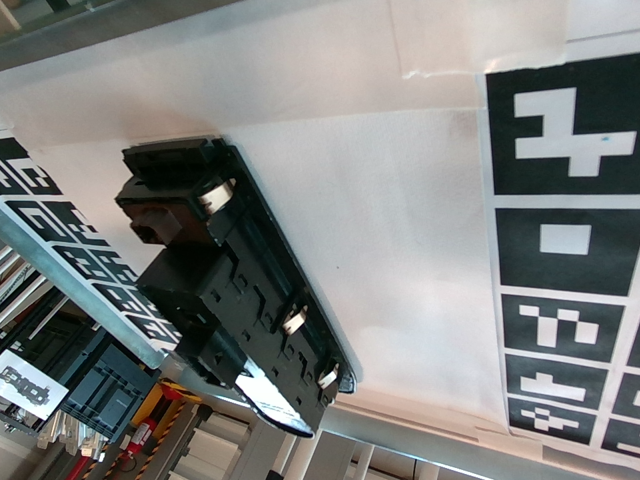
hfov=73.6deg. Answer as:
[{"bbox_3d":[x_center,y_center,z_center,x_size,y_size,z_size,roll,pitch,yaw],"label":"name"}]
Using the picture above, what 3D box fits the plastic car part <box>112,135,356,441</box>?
[{"bbox_3d":[-0.033,0.047,0.221,0.067,0.067,0.202,-4,-43,25],"label":"plastic car part"}]
